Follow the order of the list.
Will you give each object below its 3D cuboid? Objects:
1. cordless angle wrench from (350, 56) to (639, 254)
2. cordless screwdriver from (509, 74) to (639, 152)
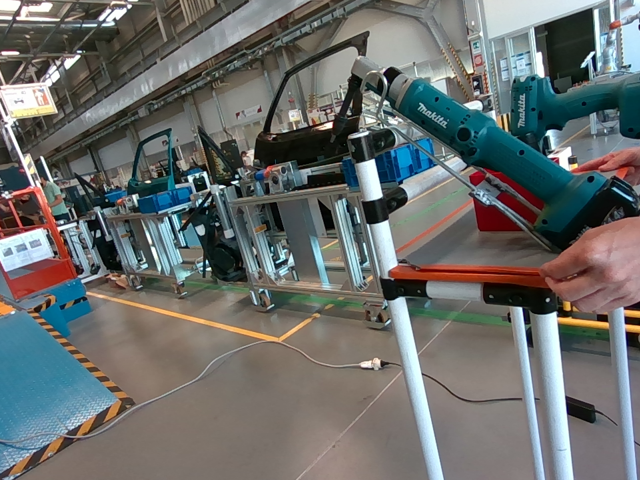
[{"bbox_3d":[0.204,-0.142,0.577,0.422,0.098,0.074,41,36,19],"label":"cordless angle wrench"},{"bbox_3d":[0.432,-0.189,0.673,0.249,0.159,0.074,10,26,40],"label":"cordless screwdriver"}]
